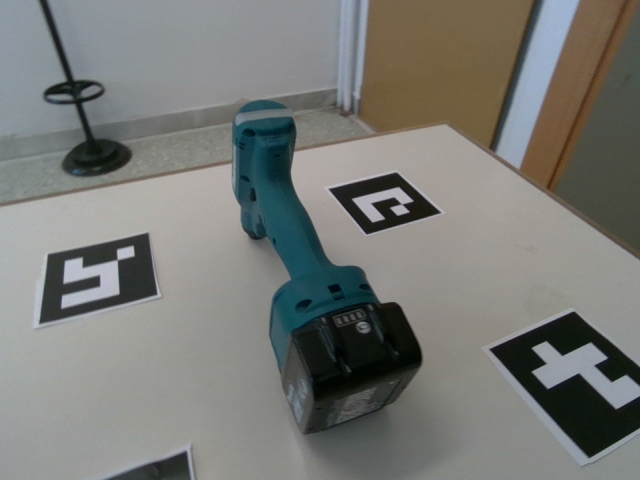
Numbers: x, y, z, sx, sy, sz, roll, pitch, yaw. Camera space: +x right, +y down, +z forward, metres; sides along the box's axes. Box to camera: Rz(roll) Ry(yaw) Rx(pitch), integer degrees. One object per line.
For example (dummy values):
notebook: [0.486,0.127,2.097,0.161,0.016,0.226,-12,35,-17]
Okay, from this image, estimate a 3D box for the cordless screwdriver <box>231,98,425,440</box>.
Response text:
cordless screwdriver: [-0.021,0.024,0.347,0.074,0.250,0.159,-12,-33,-19]
